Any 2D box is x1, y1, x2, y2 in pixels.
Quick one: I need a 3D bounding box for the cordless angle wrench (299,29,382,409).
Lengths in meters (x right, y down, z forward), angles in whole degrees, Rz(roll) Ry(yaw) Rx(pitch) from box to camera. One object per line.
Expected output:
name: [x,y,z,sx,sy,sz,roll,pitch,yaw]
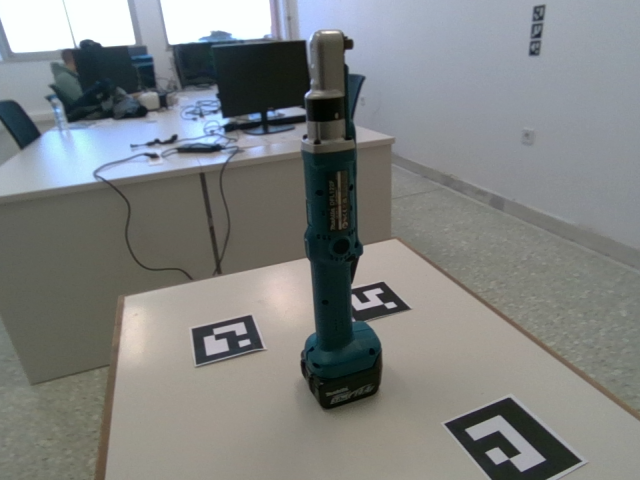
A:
cordless angle wrench: [0.014,-0.002,0.483,0.097,0.422,0.075,-11,24,-16]
